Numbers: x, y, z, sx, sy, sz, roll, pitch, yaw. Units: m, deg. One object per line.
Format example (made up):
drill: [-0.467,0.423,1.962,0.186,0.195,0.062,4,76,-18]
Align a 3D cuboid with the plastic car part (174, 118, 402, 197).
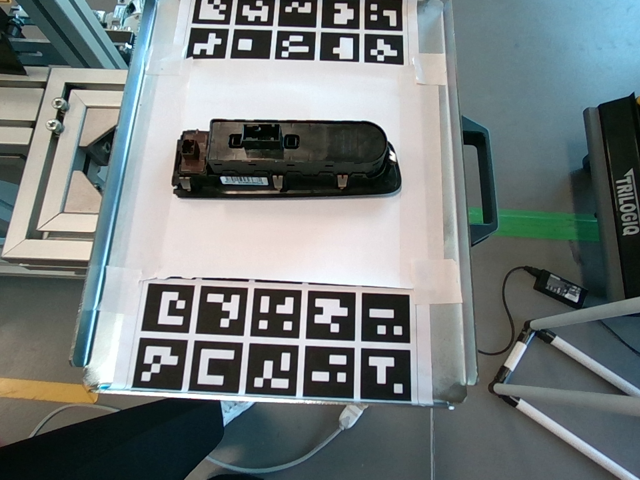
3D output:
plastic car part: [-0.027,-0.078,0.367,0.203,0.066,0.067,2,-24,-2]
